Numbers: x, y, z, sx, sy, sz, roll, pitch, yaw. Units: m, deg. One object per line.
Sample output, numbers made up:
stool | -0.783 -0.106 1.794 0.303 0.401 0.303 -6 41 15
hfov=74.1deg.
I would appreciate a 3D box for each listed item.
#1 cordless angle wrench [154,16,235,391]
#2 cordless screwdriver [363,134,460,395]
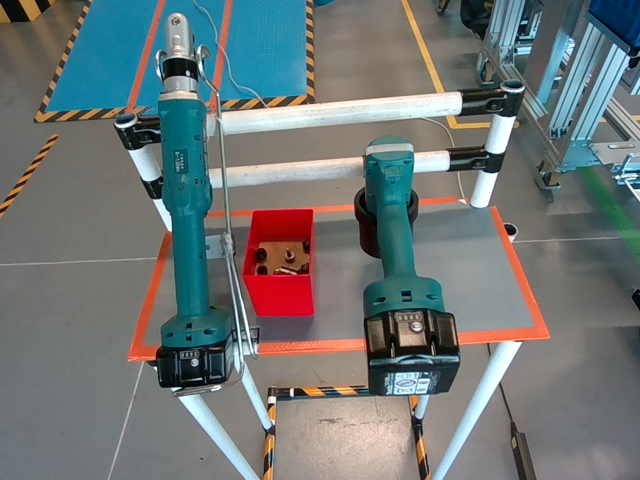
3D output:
cordless angle wrench | -0.152 -0.051 0.489 0.074 0.422 0.098 -4 -3 -5
cordless screwdriver | 0.079 0.031 0.442 0.074 0.248 0.159 -4 -33 6
